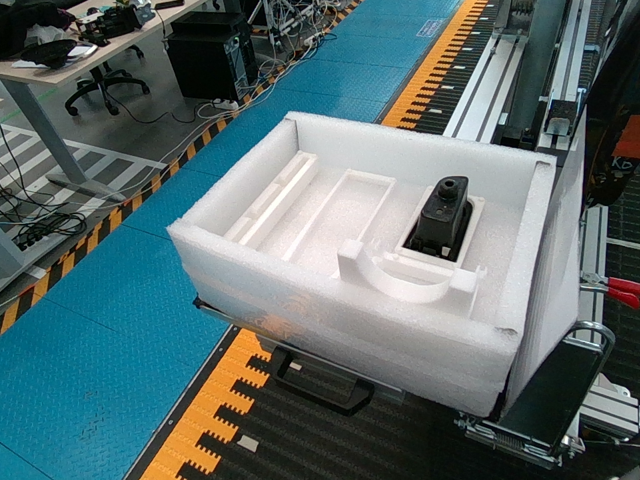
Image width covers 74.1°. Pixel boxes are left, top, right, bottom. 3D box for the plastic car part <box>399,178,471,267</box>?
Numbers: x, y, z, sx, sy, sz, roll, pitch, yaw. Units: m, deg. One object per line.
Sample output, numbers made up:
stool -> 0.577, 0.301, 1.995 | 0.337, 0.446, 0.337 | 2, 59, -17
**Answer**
plastic car part -> 0.149, -0.035, 0.518 | 0.066, 0.116, 0.071 | 18, -36, 22
